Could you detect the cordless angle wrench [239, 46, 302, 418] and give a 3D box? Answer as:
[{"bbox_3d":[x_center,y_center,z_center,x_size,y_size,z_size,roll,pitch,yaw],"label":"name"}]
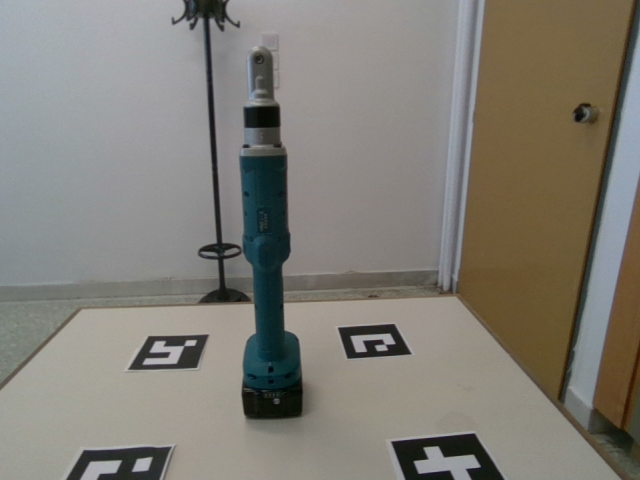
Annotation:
[{"bbox_3d":[-0.062,0.005,0.497,0.074,0.423,0.098,-2,16,-5],"label":"cordless angle wrench"}]
